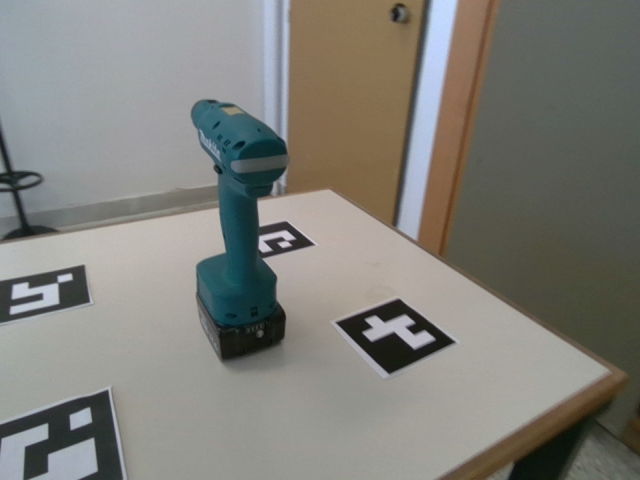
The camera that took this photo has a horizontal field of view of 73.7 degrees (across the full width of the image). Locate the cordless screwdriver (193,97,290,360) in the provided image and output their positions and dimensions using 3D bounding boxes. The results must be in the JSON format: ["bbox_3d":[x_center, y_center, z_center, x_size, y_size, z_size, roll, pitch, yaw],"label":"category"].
[{"bbox_3d":[-0.091,-0.013,0.435,0.074,0.249,0.160,-12,36,-27],"label":"cordless screwdriver"}]
